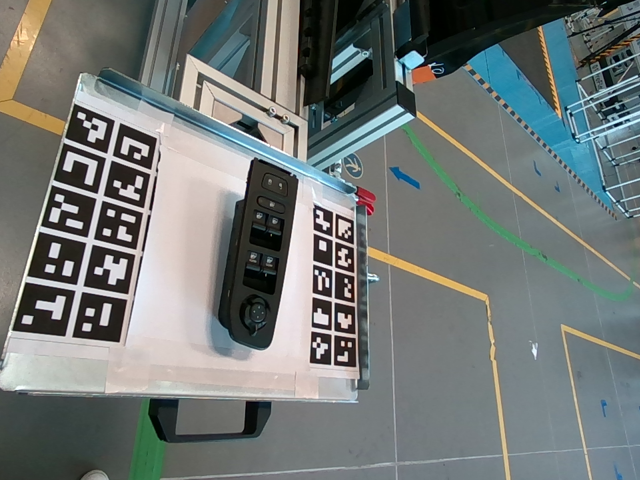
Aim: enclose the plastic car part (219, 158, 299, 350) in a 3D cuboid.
[{"bbox_3d":[-0.075,0.016,0.475,0.067,0.202,0.066,-12,-23,39],"label":"plastic car part"}]
